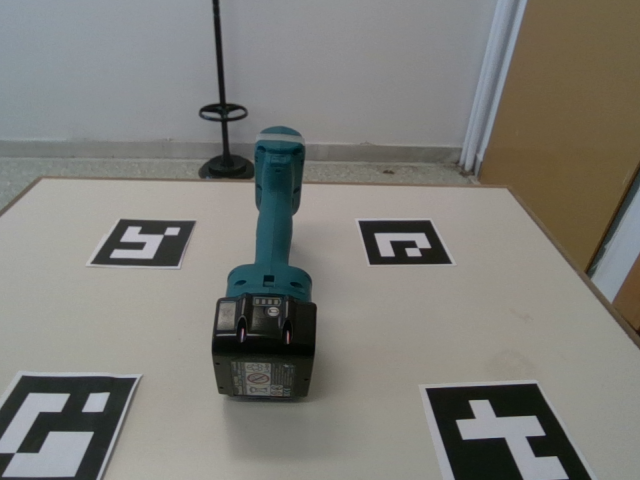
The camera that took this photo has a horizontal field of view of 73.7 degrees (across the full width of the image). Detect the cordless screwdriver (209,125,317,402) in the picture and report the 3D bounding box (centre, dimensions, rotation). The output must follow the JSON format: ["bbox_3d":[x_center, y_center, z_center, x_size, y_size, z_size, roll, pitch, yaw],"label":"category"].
[{"bbox_3d":[-0.046,0.026,0.407,0.074,0.249,0.159,4,-41,-5],"label":"cordless screwdriver"}]
